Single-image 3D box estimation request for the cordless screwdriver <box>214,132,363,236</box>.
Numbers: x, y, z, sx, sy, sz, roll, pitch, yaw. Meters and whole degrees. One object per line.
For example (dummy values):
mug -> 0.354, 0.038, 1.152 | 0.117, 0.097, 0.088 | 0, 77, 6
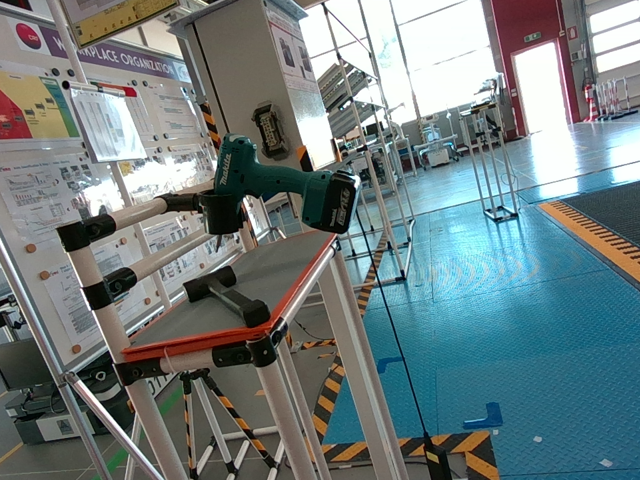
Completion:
cordless screwdriver -> -0.062, -0.069, 0.706 | 0.249, 0.159, 0.074 | 19, 21, 9
